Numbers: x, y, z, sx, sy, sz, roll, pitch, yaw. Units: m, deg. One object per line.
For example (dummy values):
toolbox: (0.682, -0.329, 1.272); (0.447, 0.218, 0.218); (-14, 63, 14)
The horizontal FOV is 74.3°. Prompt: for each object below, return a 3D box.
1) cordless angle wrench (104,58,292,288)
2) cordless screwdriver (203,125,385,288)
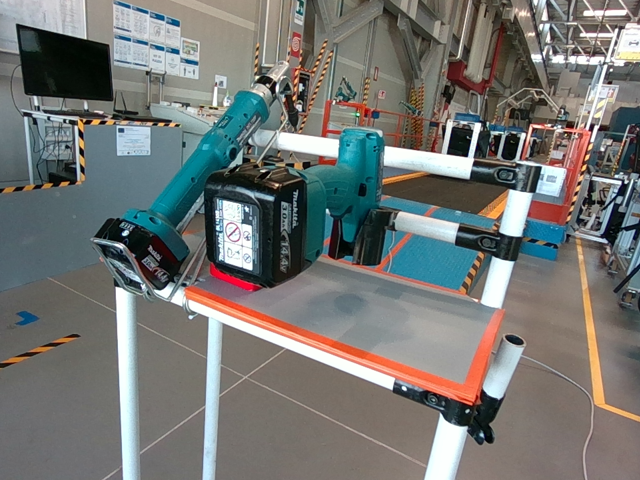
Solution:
cordless angle wrench: (-0.150, -0.131, 0.623); (0.074, 0.421, 0.098); (20, -26, 21)
cordless screwdriver: (-0.004, -0.023, 0.437); (0.074, 0.159, 0.248); (14, 27, 28)
